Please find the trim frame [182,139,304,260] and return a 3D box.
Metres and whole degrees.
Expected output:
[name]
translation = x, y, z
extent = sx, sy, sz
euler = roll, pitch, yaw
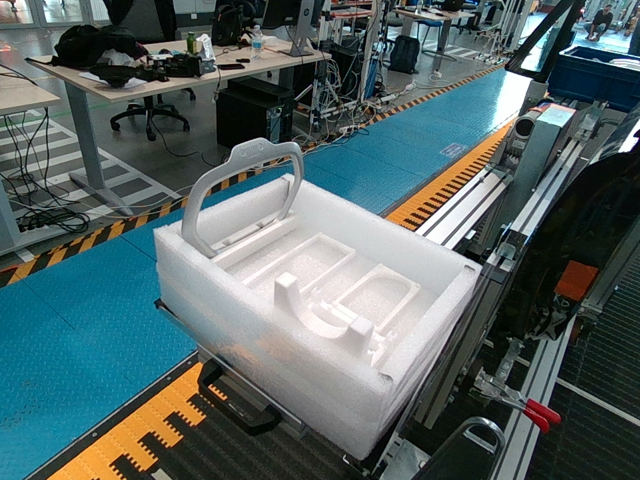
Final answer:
[trim frame]
translation = -0.110, -0.064, 0.657
extent = 0.027, 0.185, 0.247
euler = 36, 46, 26
